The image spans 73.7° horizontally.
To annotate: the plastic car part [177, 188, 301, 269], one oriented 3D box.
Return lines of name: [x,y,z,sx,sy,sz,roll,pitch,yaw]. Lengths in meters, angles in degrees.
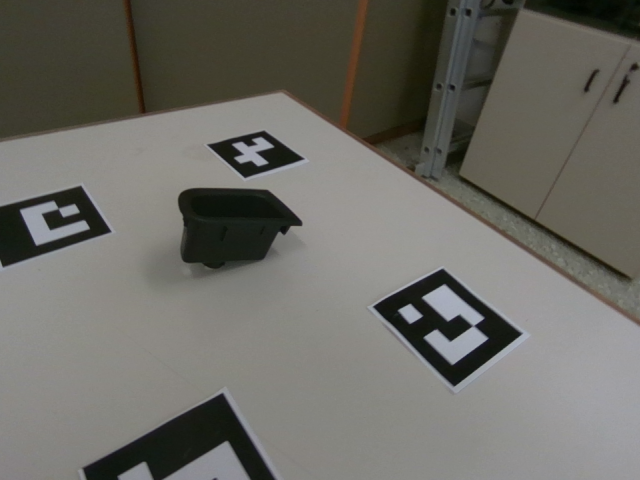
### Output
plastic car part: [-0.088,-0.006,0.407,0.115,0.071,0.066,-7,41,-43]
